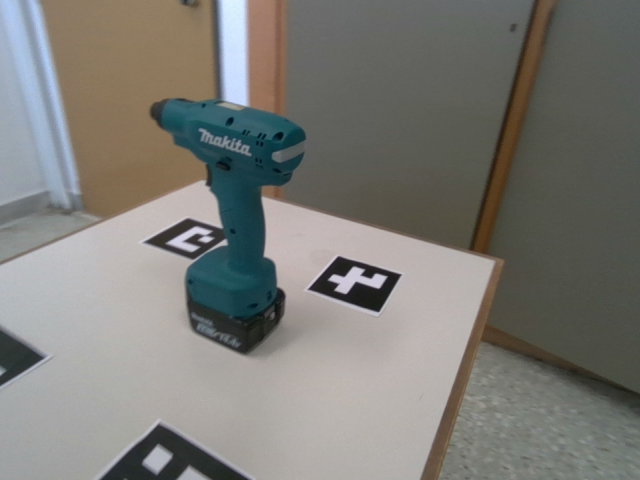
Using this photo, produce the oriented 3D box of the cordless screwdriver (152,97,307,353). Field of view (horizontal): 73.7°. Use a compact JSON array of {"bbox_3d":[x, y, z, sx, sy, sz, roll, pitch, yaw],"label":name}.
[{"bbox_3d":[-0.102,-0.015,0.438,0.160,0.249,0.074,22,32,23],"label":"cordless screwdriver"}]
